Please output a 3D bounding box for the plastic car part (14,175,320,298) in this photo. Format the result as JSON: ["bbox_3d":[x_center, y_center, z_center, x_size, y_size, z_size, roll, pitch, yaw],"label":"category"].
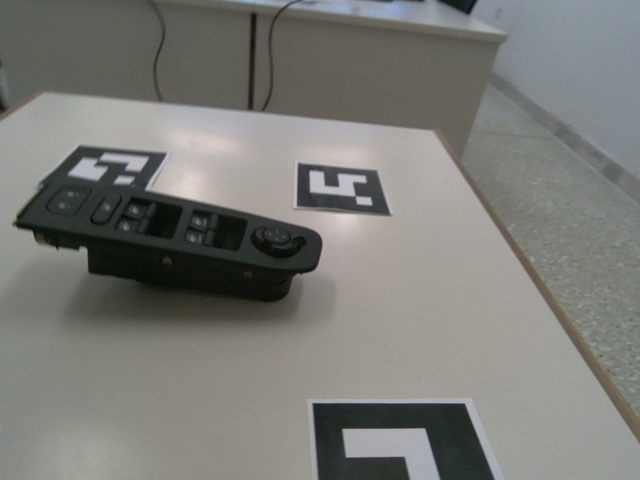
[{"bbox_3d":[-0.100,0.006,0.318,0.202,0.067,0.066,7,29,-7],"label":"plastic car part"}]
